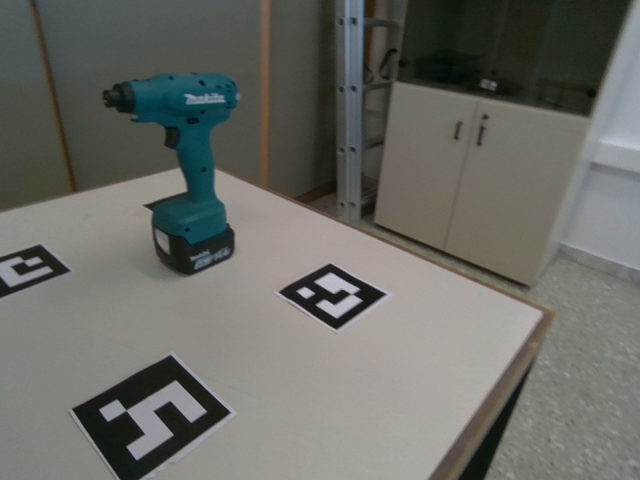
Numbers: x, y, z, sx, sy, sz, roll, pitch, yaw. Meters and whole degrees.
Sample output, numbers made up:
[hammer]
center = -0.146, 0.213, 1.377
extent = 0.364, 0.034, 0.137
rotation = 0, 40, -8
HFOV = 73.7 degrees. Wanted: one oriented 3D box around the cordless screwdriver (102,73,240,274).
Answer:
[cordless screwdriver]
center = -0.180, -0.078, 0.537
extent = 0.075, 0.249, 0.157
rotation = 26, 32, 34
